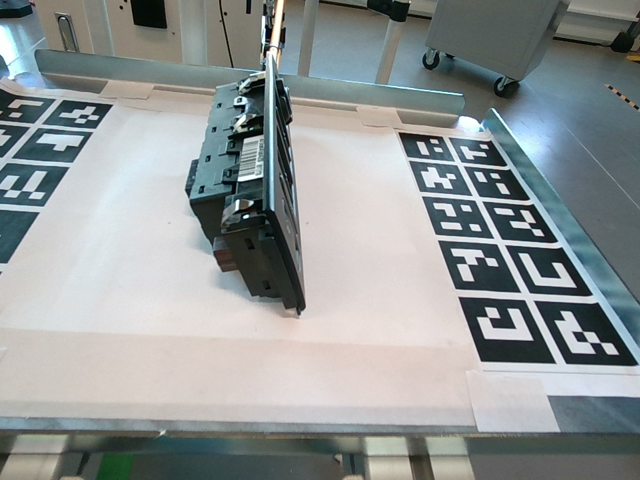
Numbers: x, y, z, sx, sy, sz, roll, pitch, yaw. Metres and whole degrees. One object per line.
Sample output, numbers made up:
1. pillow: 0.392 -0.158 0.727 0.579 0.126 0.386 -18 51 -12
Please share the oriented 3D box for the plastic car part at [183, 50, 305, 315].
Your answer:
1. plastic car part: -0.043 -0.049 0.262 0.068 0.203 0.066 -14 -47 12
